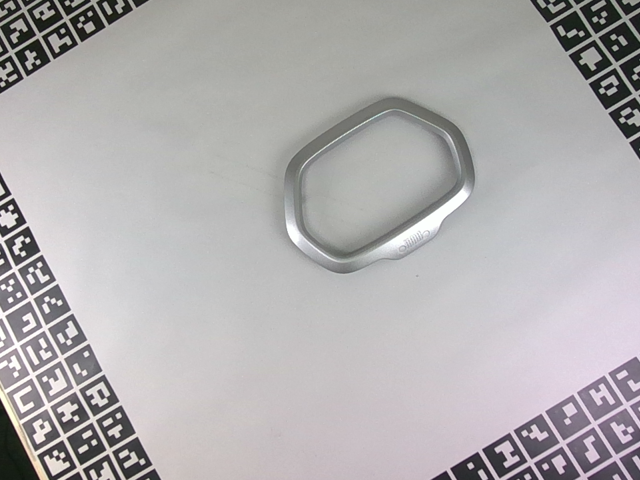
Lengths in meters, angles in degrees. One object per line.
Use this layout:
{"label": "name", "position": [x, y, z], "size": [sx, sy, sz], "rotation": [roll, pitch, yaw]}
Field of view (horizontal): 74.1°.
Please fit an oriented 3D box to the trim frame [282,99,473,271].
{"label": "trim frame", "position": [0.067, -0.069, 0.525], "size": [0.248, 0.184, 0.027], "rotation": [-33, -11, -3]}
